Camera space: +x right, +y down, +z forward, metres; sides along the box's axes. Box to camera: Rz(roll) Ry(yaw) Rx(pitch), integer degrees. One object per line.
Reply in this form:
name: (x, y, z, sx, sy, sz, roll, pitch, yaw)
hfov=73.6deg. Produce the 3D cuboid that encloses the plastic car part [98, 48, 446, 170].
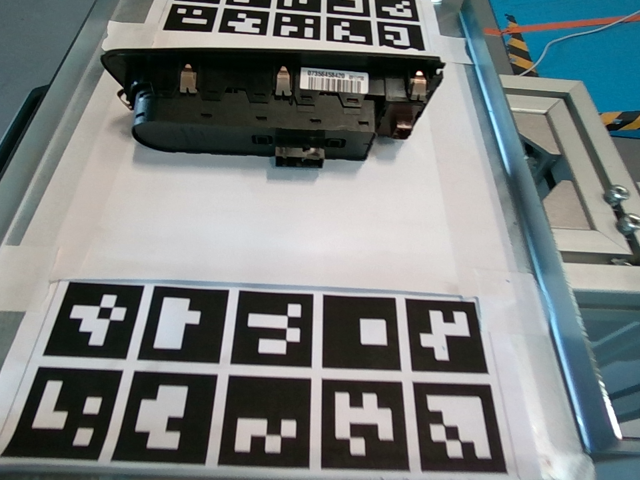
plastic car part: (-0.031, -0.079, 0.270, 0.203, 0.067, 0.066, 6, -6, -2)
